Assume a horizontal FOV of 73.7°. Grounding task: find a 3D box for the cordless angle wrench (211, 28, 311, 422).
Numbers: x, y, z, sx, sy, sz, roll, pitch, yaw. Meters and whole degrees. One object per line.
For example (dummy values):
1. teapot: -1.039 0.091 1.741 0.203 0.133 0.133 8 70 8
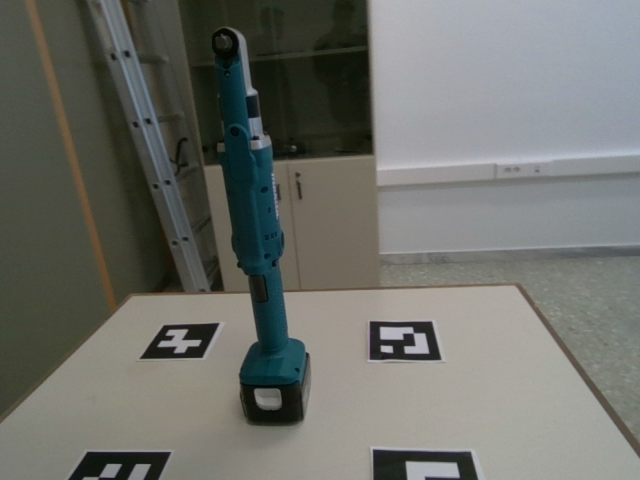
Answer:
1. cordless angle wrench: -0.068 0.004 0.465 0.074 0.422 0.098 -2 20 7
